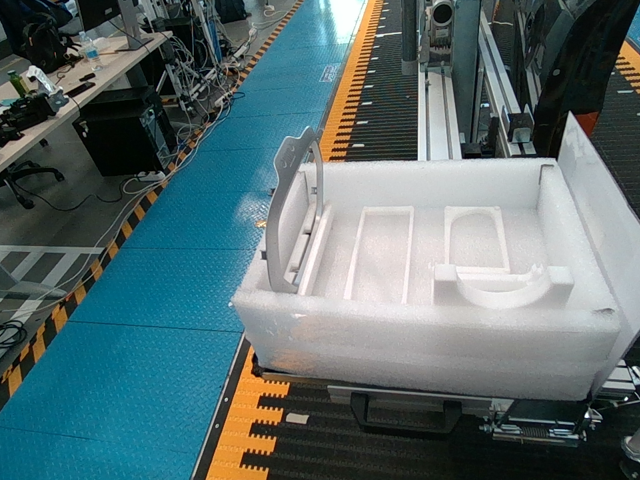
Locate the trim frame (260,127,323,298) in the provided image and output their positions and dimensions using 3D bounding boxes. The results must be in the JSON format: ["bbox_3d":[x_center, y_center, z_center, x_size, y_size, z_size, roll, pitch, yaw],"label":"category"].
[{"bbox_3d":[-0.030,-0.039,0.553,0.028,0.184,0.247,7,46,14],"label":"trim frame"}]
